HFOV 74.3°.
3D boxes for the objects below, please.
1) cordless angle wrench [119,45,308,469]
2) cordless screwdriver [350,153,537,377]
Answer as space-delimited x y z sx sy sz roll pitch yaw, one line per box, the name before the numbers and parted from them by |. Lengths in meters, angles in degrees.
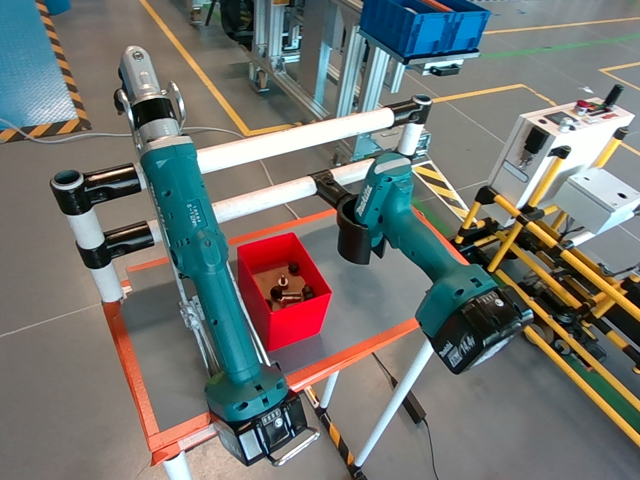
cordless angle wrench | -0.122 0.011 0.431 0.074 0.423 0.098 -20 5 -31
cordless screwdriver | 0.115 0.035 0.498 0.074 0.248 0.160 -18 -30 -25
